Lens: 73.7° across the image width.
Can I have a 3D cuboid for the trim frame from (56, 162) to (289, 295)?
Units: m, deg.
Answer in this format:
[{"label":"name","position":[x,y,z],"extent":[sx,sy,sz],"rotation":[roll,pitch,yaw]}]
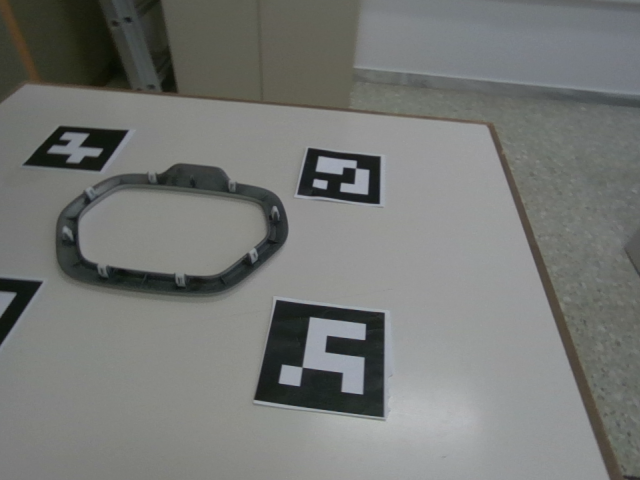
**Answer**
[{"label":"trim frame","position":[-0.156,-0.021,0.453],"extent":[0.249,0.027,0.184],"rotation":[5,45,7]}]
